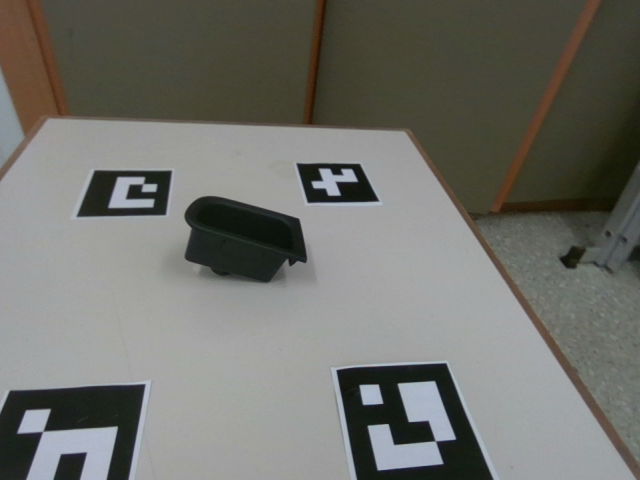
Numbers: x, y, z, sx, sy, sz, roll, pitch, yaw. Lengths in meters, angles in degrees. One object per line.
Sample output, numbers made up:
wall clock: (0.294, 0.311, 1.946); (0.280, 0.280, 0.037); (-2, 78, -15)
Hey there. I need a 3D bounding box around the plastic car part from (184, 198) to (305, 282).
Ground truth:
plastic car part: (-0.082, 0.007, 0.426); (0.115, 0.071, 0.066); (13, 39, -22)
